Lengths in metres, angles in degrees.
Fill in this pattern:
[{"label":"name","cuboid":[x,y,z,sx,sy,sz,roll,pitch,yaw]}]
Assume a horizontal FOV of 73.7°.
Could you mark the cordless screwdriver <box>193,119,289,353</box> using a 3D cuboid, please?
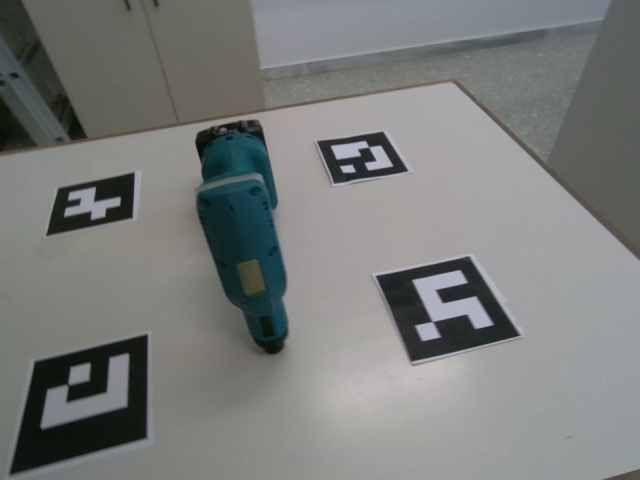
[{"label":"cordless screwdriver","cuboid":[-0.072,-0.021,0.420,0.074,0.159,0.250,-14,30,-5]}]
